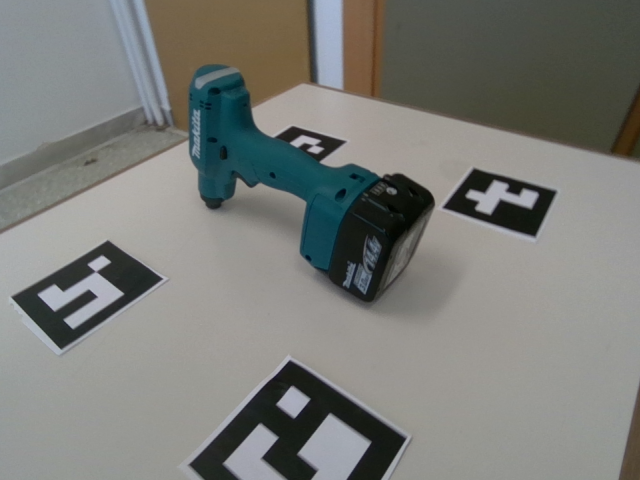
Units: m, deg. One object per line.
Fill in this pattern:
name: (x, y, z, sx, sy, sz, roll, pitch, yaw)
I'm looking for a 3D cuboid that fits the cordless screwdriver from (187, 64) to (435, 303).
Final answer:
cordless screwdriver: (-0.031, -0.039, 0.401, 0.250, 0.159, 0.074, 36, 48, 19)
